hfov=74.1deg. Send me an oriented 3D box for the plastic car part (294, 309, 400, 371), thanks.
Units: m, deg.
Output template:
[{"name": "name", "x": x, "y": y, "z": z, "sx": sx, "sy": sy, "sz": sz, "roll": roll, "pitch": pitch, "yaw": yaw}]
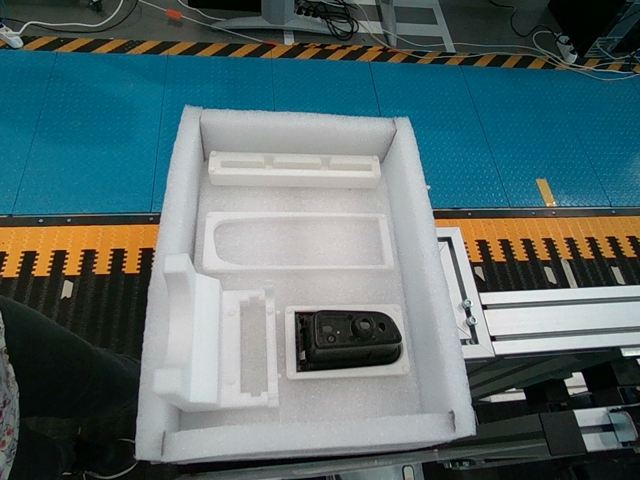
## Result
[{"name": "plastic car part", "x": 0.032, "y": 0.098, "z": 0.446, "sx": 0.116, "sy": 0.066, "sz": 0.071, "roll": -1, "pitch": -26, "yaw": -5}]
